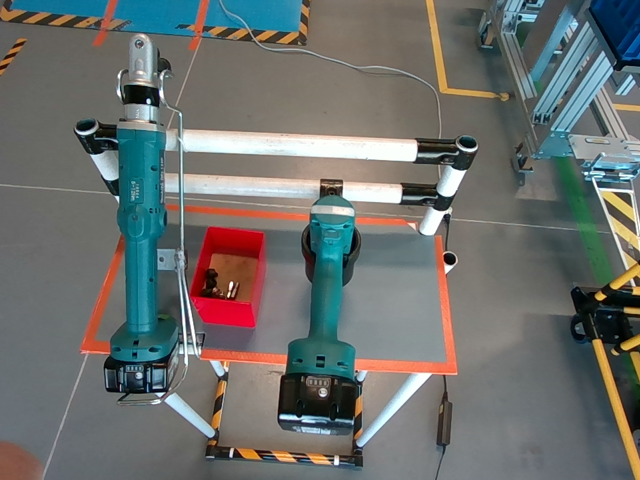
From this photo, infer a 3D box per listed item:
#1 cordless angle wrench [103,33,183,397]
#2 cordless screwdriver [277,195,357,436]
[{"bbox_3d":[-0.213,-0.026,0.513,0.074,0.423,0.098,2,8,-5],"label":"cordless angle wrench"},{"bbox_3d":[0.006,0.090,0.492,0.074,0.248,0.159,4,-23,2],"label":"cordless screwdriver"}]
